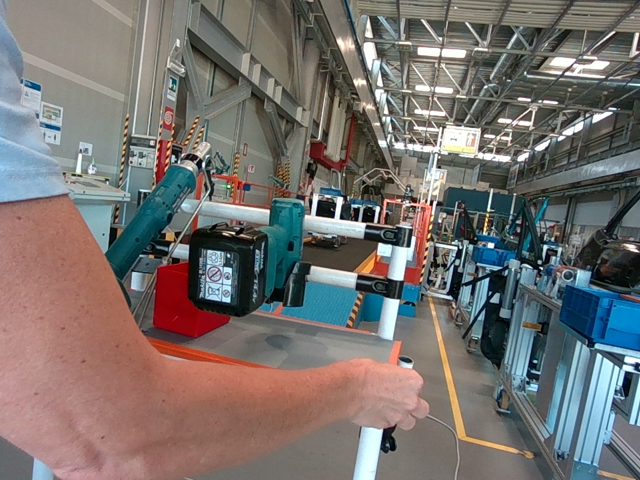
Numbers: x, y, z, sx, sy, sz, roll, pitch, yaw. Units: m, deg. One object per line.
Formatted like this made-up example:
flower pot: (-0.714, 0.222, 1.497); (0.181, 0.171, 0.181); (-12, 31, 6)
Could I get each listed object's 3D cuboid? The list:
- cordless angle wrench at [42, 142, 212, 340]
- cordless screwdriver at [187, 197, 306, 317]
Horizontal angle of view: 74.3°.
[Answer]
cordless angle wrench: (-0.277, -0.039, 0.705); (0.074, 0.421, 0.098); (13, -41, 7)
cordless screwdriver: (-0.075, 0.035, 0.548); (0.074, 0.159, 0.248); (6, 13, 13)
